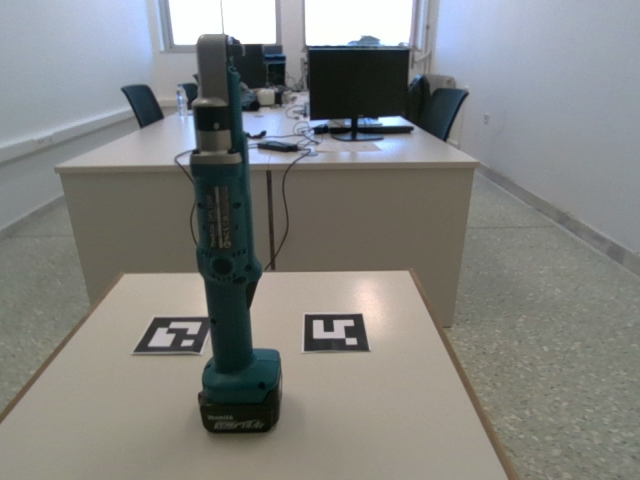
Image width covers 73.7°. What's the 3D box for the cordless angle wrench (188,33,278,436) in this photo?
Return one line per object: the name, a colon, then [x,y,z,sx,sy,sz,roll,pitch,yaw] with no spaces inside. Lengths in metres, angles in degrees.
cordless angle wrench: [-0.099,0.017,0.449,0.098,0.423,0.074,-2,22,-6]
